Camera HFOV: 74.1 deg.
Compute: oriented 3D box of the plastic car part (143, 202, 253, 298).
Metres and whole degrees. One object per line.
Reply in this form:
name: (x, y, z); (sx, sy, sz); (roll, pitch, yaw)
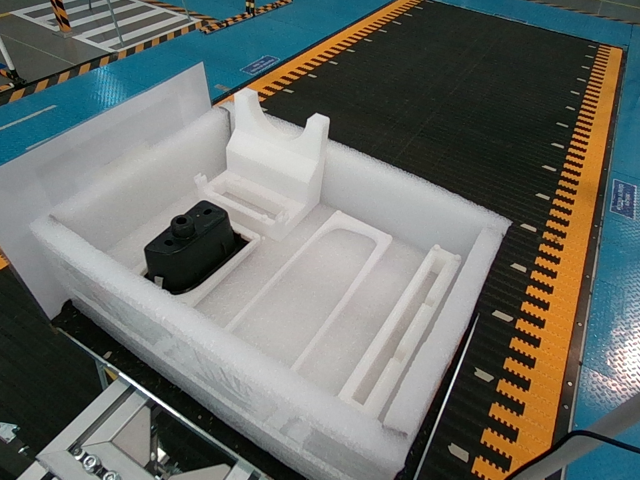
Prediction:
plastic car part: (-0.133, 0.002, 0.445); (0.066, 0.071, 0.116); (27, 47, 21)
